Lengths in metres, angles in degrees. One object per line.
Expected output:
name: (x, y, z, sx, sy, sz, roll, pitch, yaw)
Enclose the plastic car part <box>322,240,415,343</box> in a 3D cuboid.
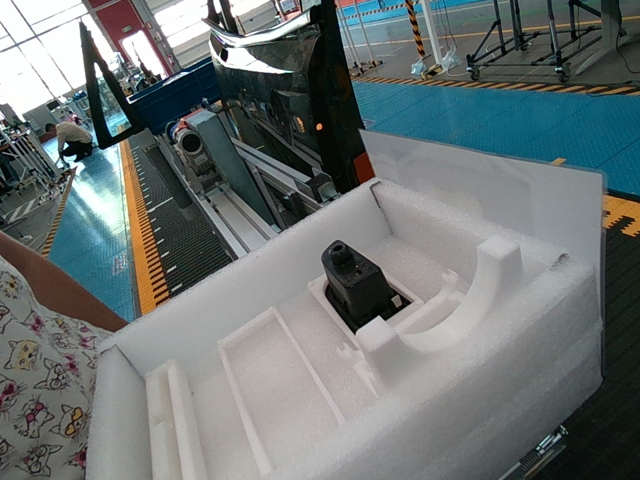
plastic car part: (0.034, 0.039, 0.446, 0.066, 0.071, 0.117, -30, 33, -9)
